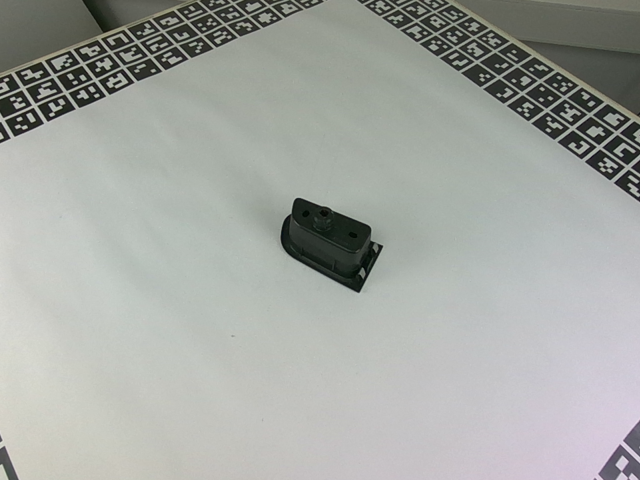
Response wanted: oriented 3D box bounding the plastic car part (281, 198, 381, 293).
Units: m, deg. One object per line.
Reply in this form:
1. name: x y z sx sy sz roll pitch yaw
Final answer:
1. plastic car part: 0.008 -0.006 0.465 0.117 0.065 0.071 27 -29 9
